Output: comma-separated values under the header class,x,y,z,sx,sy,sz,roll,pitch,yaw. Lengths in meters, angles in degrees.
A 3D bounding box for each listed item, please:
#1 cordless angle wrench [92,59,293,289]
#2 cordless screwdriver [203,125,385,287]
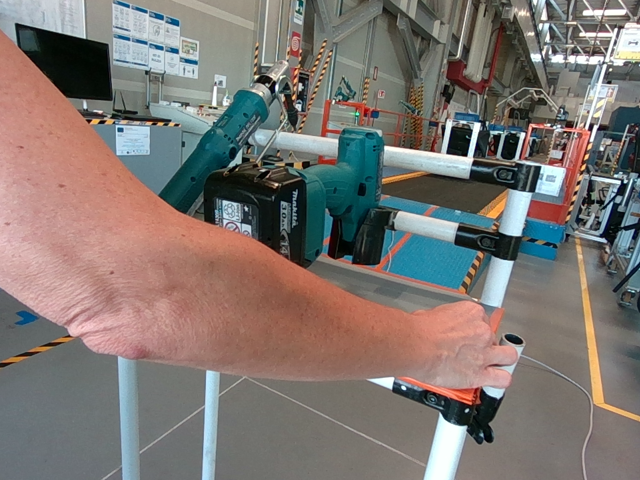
class,x,y,z,sx,sy,sz,roll,pitch,yaw
cordless angle wrench,-0.149,-0.129,0.619,0.074,0.421,0.098,19,-27,21
cordless screwdriver,-0.003,-0.023,0.437,0.074,0.159,0.248,14,27,28
